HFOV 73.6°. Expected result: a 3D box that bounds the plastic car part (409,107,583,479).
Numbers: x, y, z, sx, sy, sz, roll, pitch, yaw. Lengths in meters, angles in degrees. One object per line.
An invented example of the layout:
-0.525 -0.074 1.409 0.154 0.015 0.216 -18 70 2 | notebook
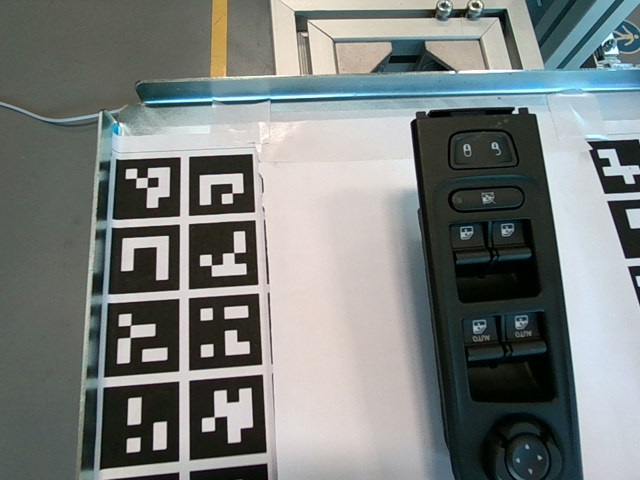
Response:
0.081 0.038 0.221 0.066 0.202 0.067 -3 -12 -13 | plastic car part
